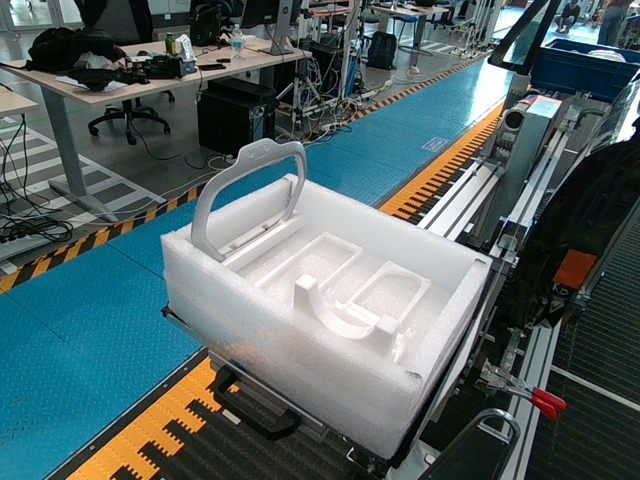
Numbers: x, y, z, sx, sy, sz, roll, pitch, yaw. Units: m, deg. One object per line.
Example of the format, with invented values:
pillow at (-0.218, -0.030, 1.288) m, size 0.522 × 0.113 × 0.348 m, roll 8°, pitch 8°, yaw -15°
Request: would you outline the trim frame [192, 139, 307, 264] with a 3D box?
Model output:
trim frame at (-0.098, -0.061, 0.651) m, size 0.027 × 0.184 × 0.247 m, roll 33°, pitch 45°, yaw 24°
